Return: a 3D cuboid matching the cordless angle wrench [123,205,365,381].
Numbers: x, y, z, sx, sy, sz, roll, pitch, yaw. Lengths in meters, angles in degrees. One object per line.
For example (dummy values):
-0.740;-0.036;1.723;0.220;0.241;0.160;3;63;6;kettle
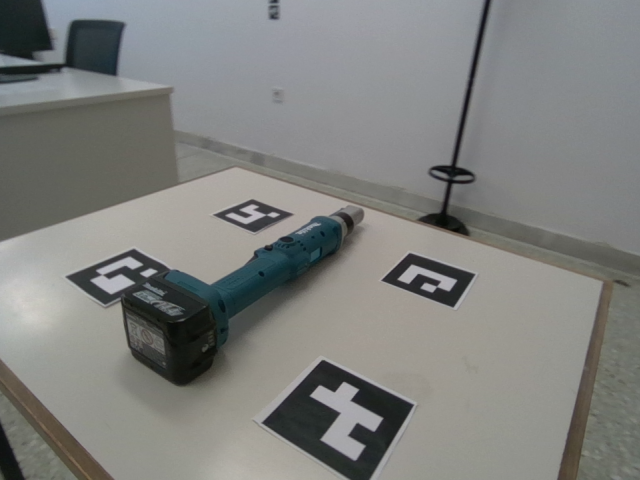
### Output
-0.048;0.024;0.570;0.099;0.074;0.419;20;31;29;cordless angle wrench
